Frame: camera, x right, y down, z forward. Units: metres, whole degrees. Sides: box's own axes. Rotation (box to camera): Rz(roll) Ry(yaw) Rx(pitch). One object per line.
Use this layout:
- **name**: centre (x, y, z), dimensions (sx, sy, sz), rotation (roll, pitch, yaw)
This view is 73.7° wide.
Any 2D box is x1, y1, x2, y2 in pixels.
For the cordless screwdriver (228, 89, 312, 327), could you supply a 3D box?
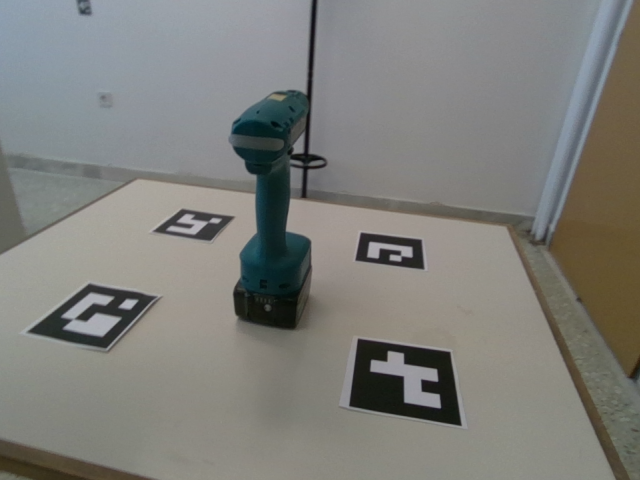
- **cordless screwdriver**: centre (-0.044, -0.037, 0.475), dimensions (0.074, 0.249, 0.158), rotation (9, 32, 9)
